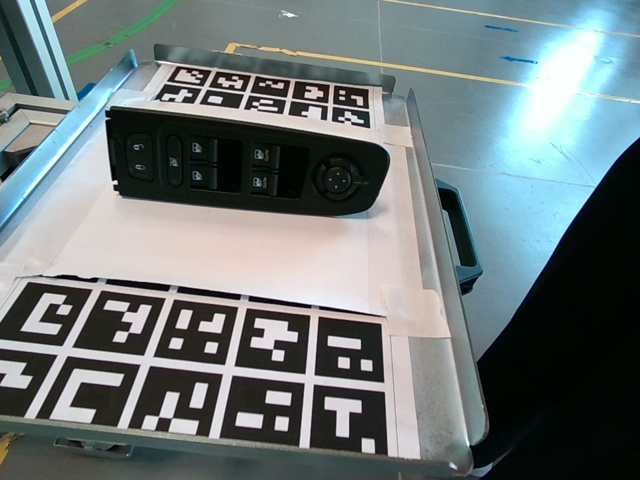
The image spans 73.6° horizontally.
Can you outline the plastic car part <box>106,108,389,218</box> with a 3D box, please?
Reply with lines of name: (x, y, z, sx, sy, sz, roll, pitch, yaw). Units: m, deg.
plastic car part: (-0.051, -0.058, 0.334, 0.203, 0.067, 0.067, 7, 18, 0)
